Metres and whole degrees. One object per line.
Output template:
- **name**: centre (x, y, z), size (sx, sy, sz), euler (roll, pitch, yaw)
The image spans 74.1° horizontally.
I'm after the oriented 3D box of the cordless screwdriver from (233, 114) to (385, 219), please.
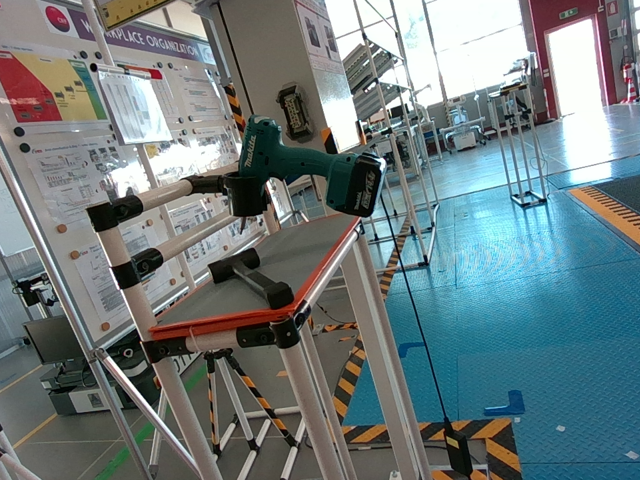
- **cordless screwdriver**: centre (-0.028, -0.096, 0.698), size (0.249, 0.159, 0.074), euler (20, 22, 12)
